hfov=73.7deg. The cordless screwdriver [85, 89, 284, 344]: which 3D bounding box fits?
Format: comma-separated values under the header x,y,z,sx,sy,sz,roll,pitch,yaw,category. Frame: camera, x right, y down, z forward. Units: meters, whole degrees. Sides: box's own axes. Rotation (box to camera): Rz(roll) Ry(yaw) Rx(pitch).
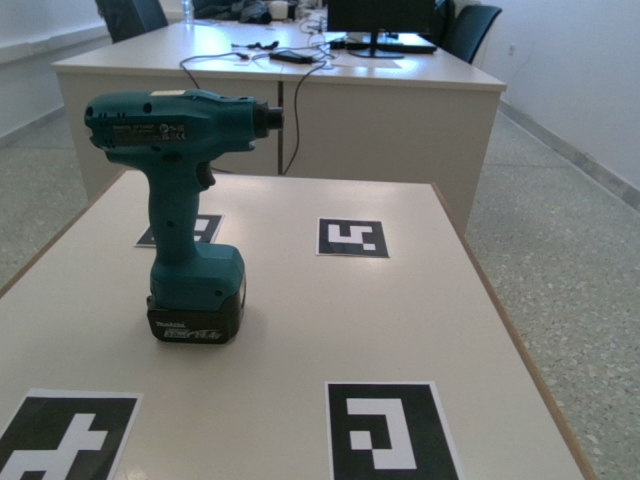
x,y,z,sx,sy,sz,roll,pitch,yaw,category
-0.108,-0.015,0.411,0.159,0.248,0.074,0,31,2,cordless screwdriver
